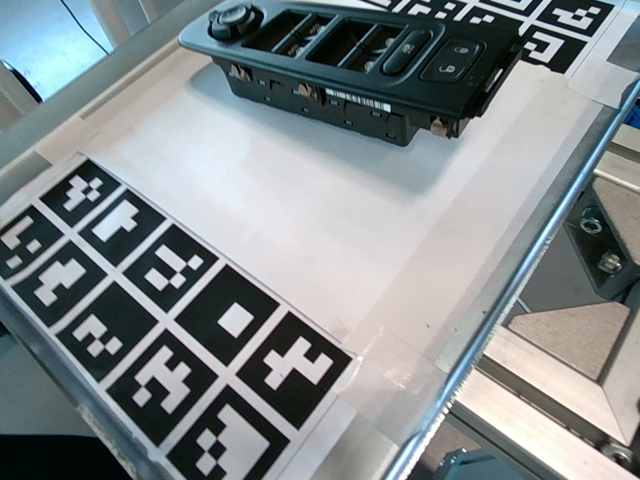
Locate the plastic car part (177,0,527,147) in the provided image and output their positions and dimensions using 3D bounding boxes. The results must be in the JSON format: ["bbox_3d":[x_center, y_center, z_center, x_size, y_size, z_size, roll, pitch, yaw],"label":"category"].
[{"bbox_3d":[0.004,-0.102,0.253,0.204,0.066,0.067,26,-16,25],"label":"plastic car part"}]
